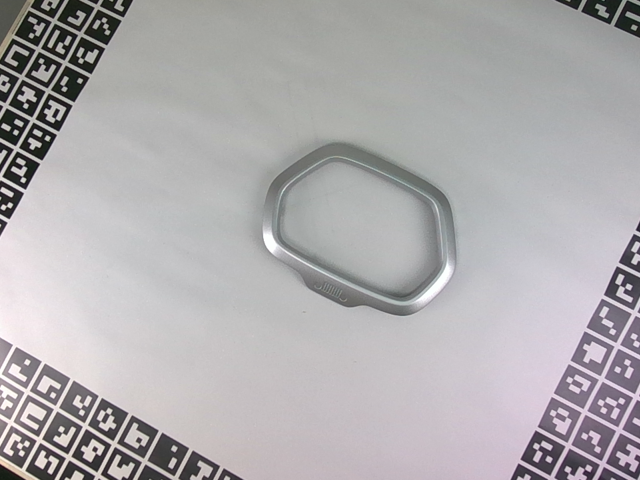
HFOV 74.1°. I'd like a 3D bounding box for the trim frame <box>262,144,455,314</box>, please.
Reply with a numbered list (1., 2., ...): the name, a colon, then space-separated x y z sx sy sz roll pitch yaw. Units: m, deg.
1. trim frame: 0.048 -0.012 0.524 0.248 0.184 0.027 25 -2 1
